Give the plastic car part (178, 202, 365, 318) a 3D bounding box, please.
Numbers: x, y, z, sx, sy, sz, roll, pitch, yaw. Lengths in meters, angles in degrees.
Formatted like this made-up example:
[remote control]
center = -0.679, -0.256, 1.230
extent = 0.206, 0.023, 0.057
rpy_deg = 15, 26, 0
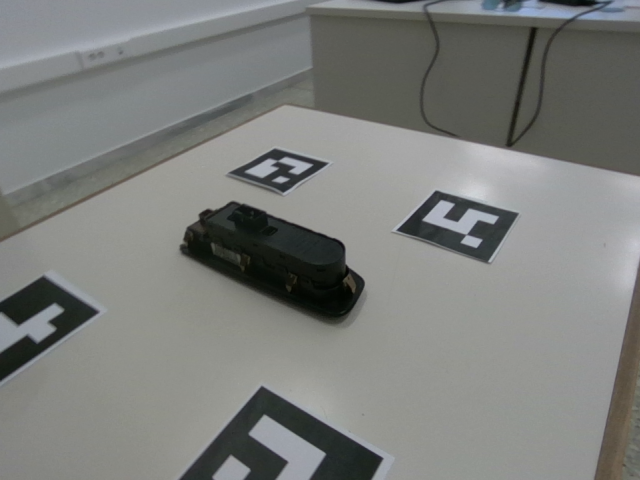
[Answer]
[plastic car part]
center = -0.048, 0.006, 0.399
extent = 0.205, 0.067, 0.066
rpy_deg = 23, 35, 29
